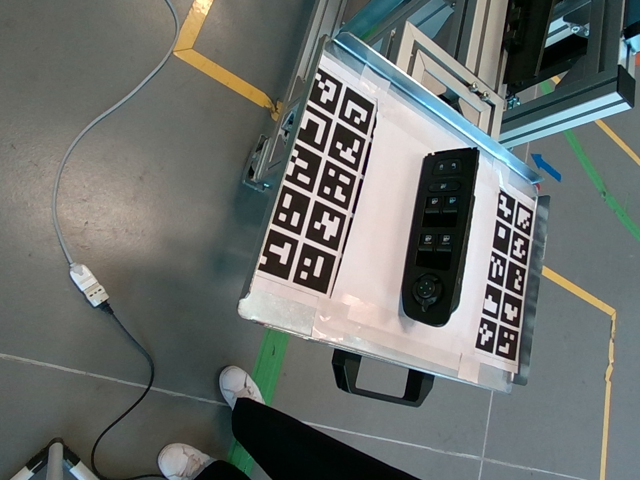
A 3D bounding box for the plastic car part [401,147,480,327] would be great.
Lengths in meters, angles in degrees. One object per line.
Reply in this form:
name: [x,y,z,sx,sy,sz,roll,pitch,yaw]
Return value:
plastic car part: [0.138,-0.001,0.485,0.067,0.203,0.067,5,-20,32]
